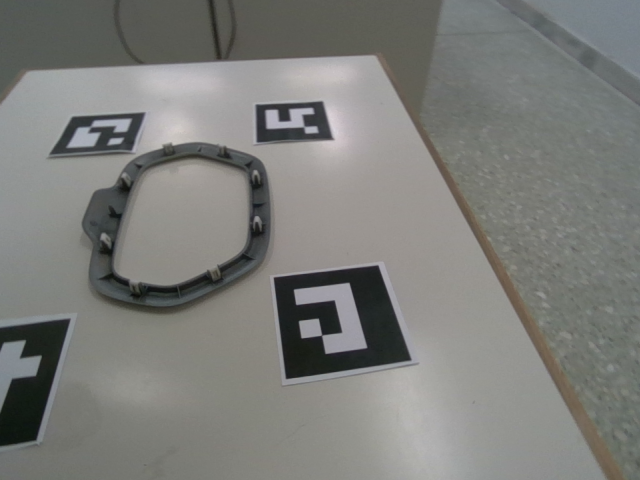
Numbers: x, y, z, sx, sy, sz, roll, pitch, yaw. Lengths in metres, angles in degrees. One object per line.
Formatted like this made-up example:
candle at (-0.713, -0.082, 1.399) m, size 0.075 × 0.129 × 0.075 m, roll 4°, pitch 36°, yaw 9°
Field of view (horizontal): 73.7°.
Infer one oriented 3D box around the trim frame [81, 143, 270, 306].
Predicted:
trim frame at (-0.145, -0.034, 0.444) m, size 0.184 × 0.249 × 0.027 m, roll -5°, pitch -43°, yaw -4°
